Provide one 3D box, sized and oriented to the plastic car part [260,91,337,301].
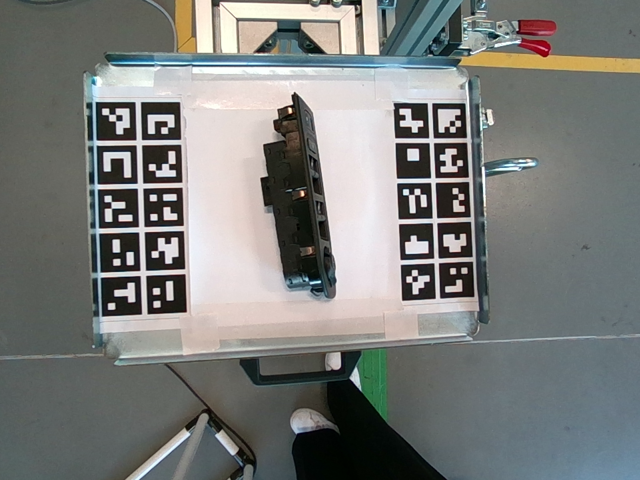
[{"bbox_3d":[-0.022,-0.036,0.425,0.067,0.203,0.066,-13,-5,4],"label":"plastic car part"}]
